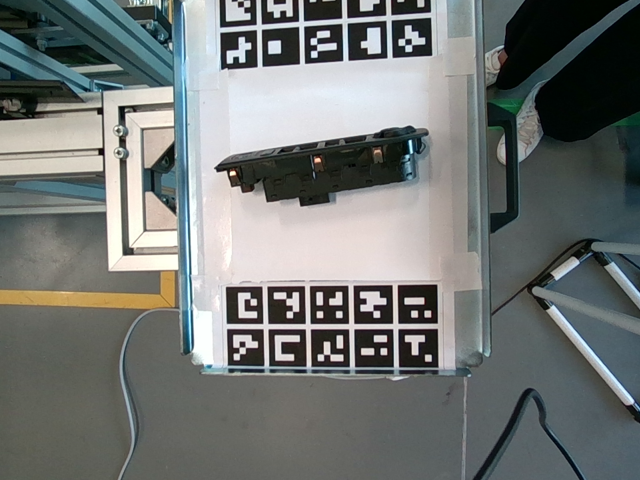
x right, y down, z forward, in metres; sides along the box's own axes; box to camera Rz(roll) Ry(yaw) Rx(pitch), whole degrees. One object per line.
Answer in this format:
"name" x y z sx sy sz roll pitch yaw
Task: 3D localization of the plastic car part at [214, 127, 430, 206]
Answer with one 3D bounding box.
"plastic car part" 0.008 -0.070 0.413 0.203 0.067 0.066 -12 11 6
